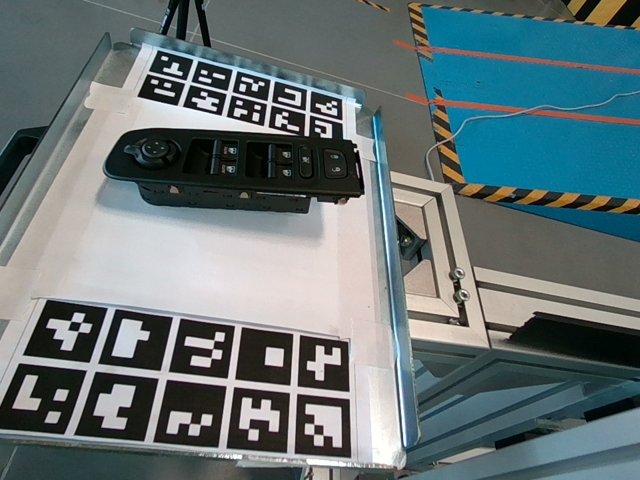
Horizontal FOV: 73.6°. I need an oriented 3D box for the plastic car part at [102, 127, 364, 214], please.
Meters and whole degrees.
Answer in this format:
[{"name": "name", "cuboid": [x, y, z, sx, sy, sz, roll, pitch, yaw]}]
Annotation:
[{"name": "plastic car part", "cuboid": [-0.070, -0.056, 0.363, 0.202, 0.066, 0.067, 5, -28, -12]}]
